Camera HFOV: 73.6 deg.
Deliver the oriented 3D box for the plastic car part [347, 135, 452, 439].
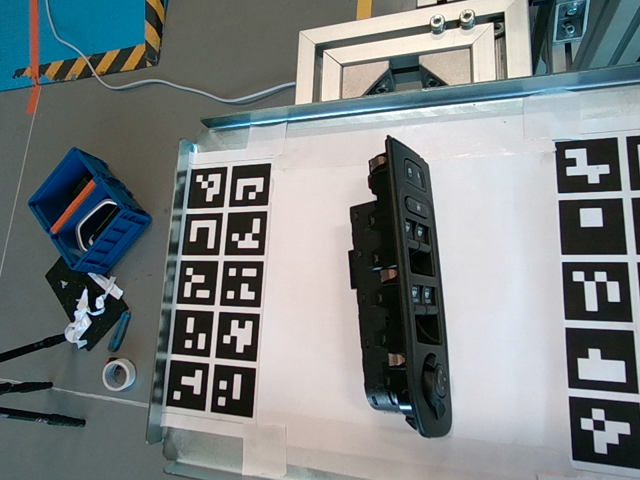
[{"bbox_3d":[0.053,0.034,0.303,0.067,0.202,0.066,-14,-15,25],"label":"plastic car part"}]
